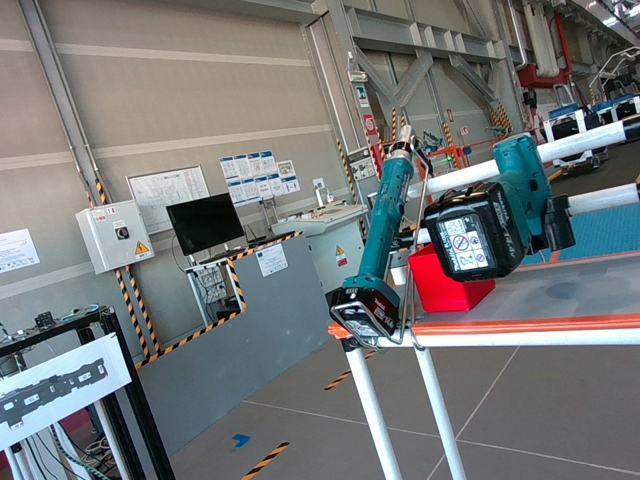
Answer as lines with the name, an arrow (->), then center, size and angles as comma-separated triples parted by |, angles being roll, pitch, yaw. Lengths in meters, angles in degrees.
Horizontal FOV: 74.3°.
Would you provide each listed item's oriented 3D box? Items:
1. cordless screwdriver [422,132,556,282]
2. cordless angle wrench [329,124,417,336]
cordless screwdriver -> 0.224, -0.024, 0.505 | 0.074, 0.159, 0.248 | -14, 14, 44
cordless angle wrench -> 0.119, -0.046, 0.735 | 0.074, 0.421, 0.098 | -8, -37, 39
